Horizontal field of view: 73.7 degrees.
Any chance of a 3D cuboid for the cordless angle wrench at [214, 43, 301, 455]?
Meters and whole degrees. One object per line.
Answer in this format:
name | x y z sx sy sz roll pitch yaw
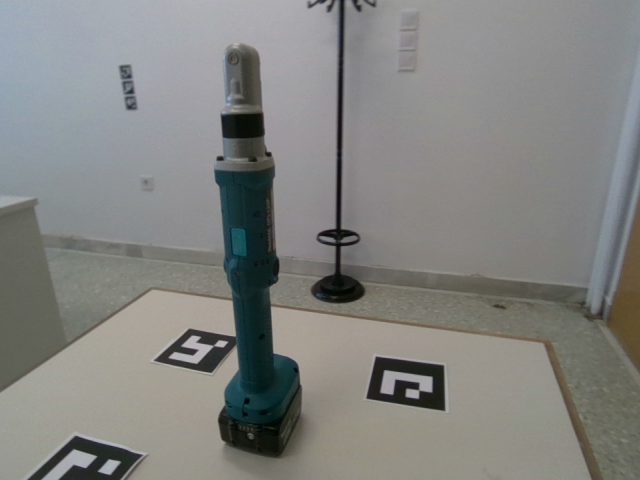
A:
cordless angle wrench | -0.071 0.026 0.445 0.075 0.423 0.097 5 20 16
